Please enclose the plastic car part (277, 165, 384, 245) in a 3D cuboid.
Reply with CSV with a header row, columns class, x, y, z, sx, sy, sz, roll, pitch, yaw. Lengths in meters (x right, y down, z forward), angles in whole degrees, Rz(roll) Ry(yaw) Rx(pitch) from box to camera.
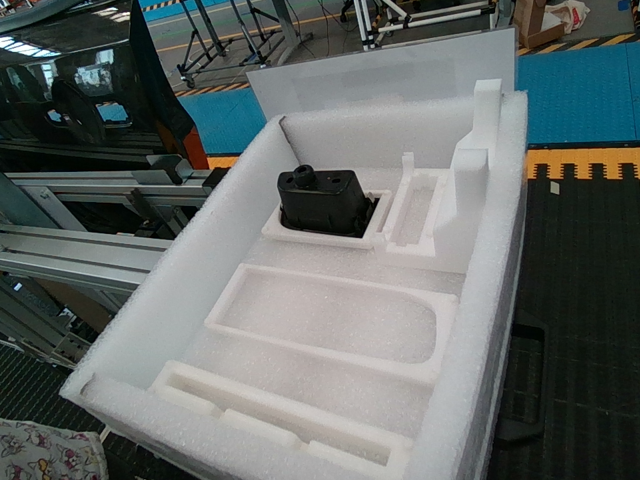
class,x,y,z,sx,sy,sz,roll,pitch,yaw
plastic car part,-0.002,-0.045,0.448,0.117,0.071,0.065,9,49,28
